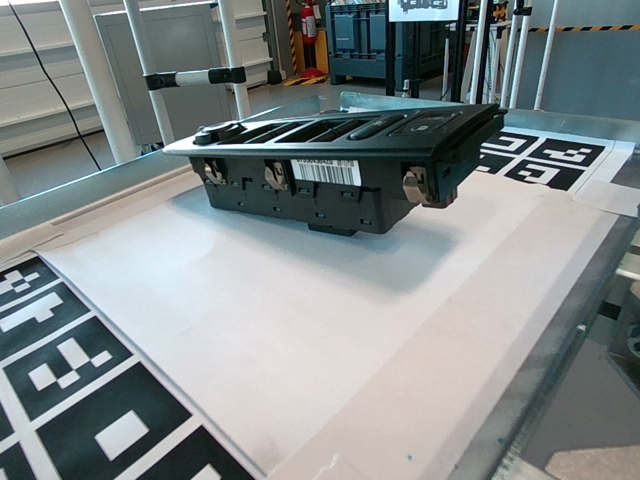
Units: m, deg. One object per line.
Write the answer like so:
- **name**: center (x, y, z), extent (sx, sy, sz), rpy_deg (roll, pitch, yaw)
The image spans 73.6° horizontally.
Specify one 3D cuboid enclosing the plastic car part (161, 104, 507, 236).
- **plastic car part**: center (-0.010, -0.040, 0.240), extent (0.204, 0.067, 0.066), rpy_deg (14, 44, 37)
